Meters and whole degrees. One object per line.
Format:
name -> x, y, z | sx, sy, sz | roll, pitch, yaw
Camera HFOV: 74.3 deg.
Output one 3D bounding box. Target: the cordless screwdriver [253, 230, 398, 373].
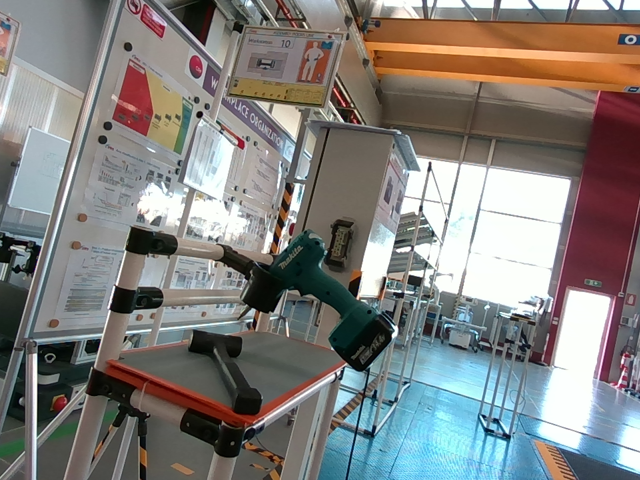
cordless screwdriver -> 0.004, 0.119, 0.729 | 0.248, 0.159, 0.074 | 47, 8, 16
